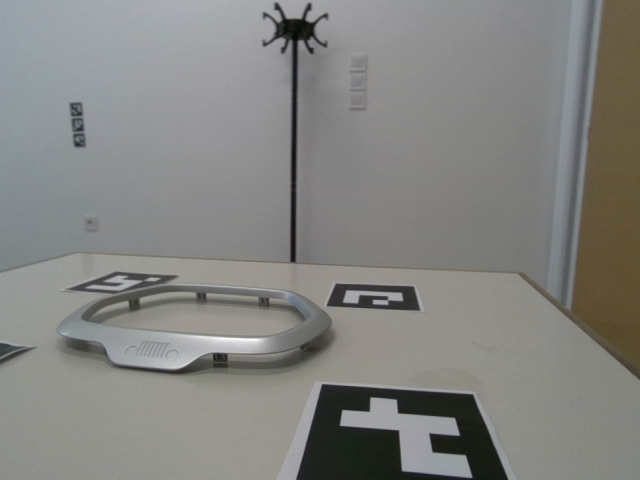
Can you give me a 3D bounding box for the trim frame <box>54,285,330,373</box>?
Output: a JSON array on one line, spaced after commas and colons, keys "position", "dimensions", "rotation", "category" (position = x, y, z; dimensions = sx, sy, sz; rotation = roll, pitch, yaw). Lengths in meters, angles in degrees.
[{"position": [-0.114, 0.075, 0.403], "dimensions": [0.249, 0.027, 0.183], "rotation": [4, 8, 9], "category": "trim frame"}]
